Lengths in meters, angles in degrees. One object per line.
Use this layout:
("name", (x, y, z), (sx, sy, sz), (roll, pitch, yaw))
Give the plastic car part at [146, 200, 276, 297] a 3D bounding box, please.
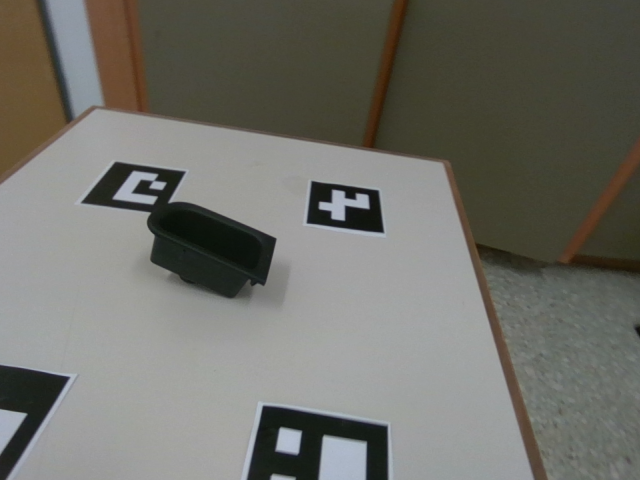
("plastic car part", (-0.112, 0.015, 0.413), (0.116, 0.066, 0.071), (24, -49, -13))
